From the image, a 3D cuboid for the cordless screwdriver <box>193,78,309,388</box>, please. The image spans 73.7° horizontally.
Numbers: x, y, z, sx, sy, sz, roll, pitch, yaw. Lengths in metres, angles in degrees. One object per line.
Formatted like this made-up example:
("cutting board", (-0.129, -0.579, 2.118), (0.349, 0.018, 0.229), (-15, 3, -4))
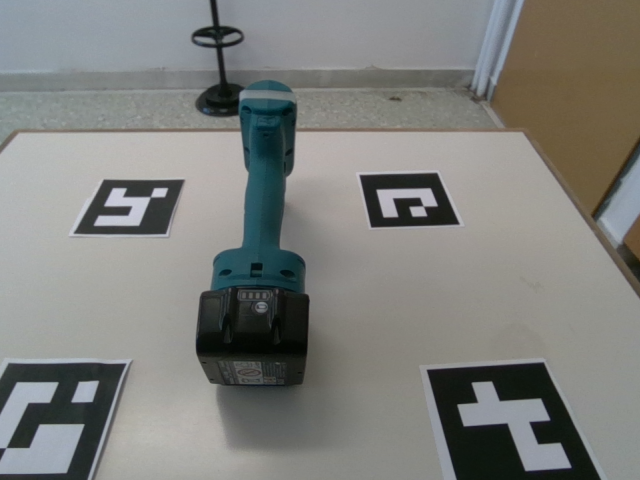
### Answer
("cordless screwdriver", (-0.051, 0.001, 0.379), (0.074, 0.249, 0.159), (2, -30, -5))
